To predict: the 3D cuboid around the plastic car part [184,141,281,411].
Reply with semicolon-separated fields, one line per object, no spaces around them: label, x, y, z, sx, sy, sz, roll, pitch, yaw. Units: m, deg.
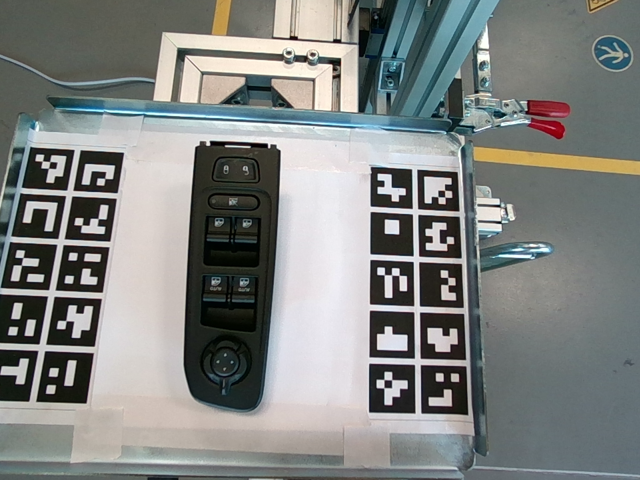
plastic car part;-0.071;0.028;0.342;0.066;0.202;0.067;3;-10;-10
